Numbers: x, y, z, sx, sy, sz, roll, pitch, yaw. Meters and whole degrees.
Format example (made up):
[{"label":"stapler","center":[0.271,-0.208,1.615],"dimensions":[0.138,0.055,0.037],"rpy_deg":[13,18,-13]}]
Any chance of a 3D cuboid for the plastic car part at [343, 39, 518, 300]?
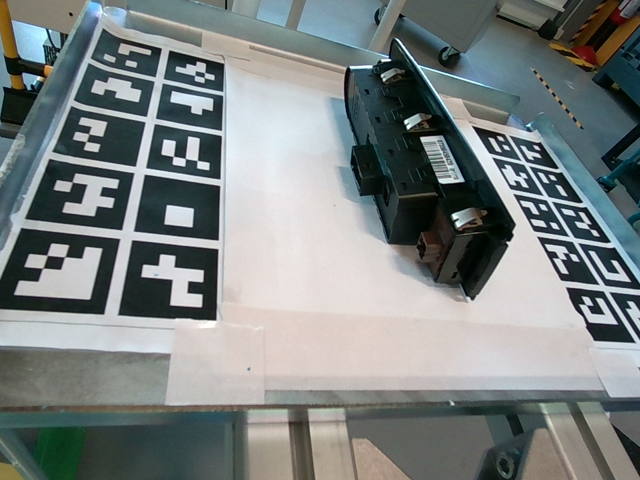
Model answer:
[{"label":"plastic car part","center":[0.052,-0.060,0.283],"dimensions":[0.067,0.202,0.066],"rpy_deg":[-7,-38,0]}]
